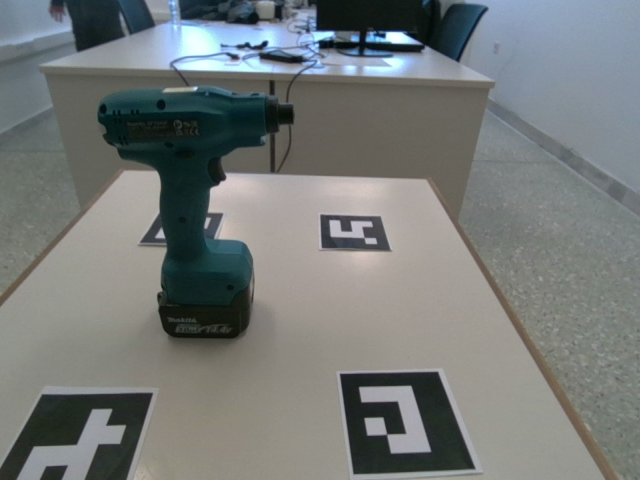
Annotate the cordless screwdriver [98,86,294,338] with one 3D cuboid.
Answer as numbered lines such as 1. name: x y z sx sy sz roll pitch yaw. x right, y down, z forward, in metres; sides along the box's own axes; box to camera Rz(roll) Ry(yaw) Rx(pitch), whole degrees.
1. cordless screwdriver: -0.100 -0.020 0.417 0.159 0.248 0.074 -1 31 1
